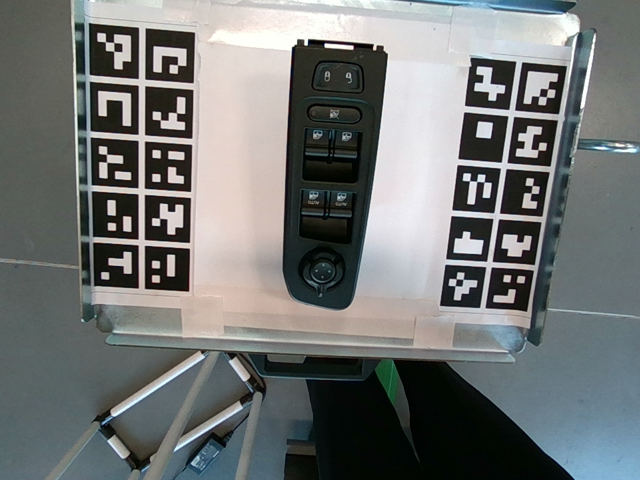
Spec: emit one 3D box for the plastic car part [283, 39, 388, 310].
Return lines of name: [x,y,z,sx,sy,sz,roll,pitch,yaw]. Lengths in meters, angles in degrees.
plastic car part: [0.003,-0.044,0.341,0.066,0.203,0.067,1,14,-11]
